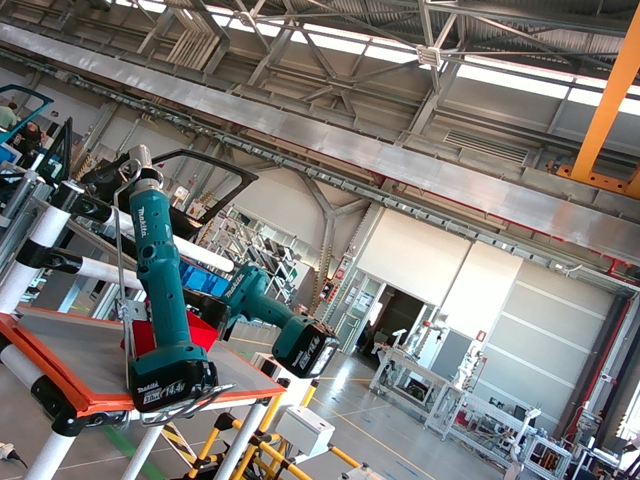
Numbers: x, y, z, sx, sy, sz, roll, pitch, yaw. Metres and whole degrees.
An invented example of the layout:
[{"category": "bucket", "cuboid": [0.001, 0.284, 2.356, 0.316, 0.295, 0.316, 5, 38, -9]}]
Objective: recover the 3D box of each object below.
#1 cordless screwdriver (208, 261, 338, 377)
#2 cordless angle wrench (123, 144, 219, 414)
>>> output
[{"category": "cordless screwdriver", "cuboid": [-0.100, 0.167, 0.800, 0.248, 0.159, 0.074, 35, 0, 26]}, {"category": "cordless angle wrench", "cuboid": [-0.242, 0.029, 0.627, 0.098, 0.422, 0.074, -21, -23, 6]}]
